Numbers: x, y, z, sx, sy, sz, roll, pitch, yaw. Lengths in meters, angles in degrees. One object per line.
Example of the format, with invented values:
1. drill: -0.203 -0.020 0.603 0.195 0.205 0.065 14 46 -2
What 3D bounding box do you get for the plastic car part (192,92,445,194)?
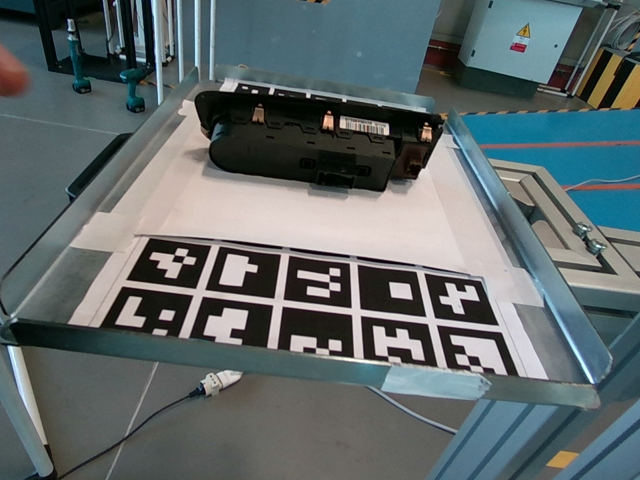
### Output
1. plastic car part: -0.005 -0.073 0.353 0.203 0.067 0.067 10 -27 -3
